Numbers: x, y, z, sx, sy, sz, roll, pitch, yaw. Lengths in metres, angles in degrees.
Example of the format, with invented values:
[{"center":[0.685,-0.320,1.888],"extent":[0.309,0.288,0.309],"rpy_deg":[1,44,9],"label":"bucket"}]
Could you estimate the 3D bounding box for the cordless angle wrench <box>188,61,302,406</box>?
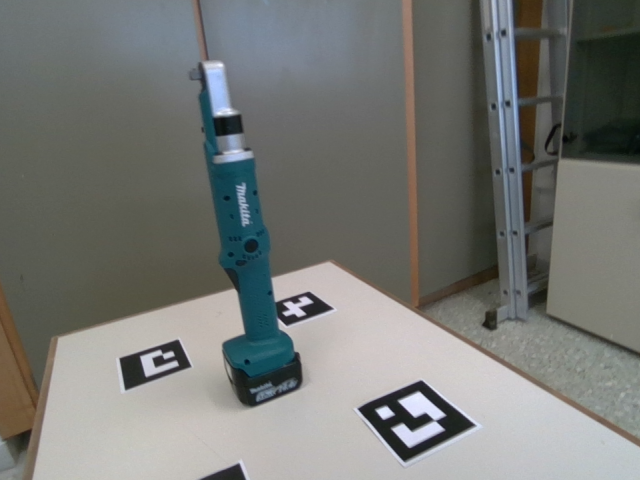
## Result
[{"center":[-0.097,0.003,0.535],"extent":[0.097,0.422,0.075],"rpy_deg":[-14,19,-24],"label":"cordless angle wrench"}]
